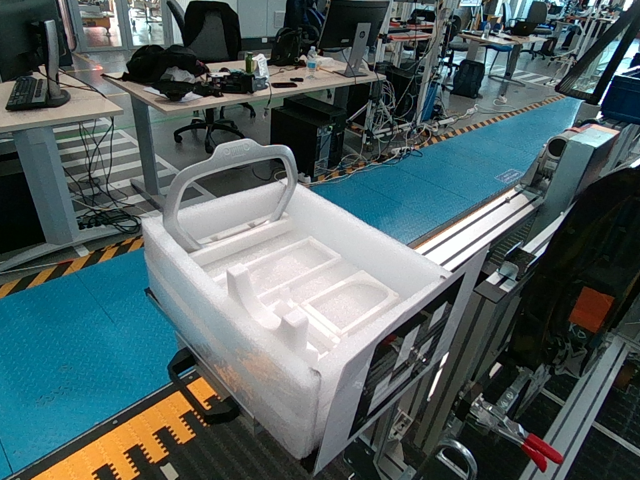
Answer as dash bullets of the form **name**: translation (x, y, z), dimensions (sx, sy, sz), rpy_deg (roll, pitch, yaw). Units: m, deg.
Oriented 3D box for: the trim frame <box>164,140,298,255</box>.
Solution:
- **trim frame**: translation (-0.132, -0.068, 0.675), dimensions (0.247, 0.184, 0.027), rpy_deg (-24, 50, -34)
